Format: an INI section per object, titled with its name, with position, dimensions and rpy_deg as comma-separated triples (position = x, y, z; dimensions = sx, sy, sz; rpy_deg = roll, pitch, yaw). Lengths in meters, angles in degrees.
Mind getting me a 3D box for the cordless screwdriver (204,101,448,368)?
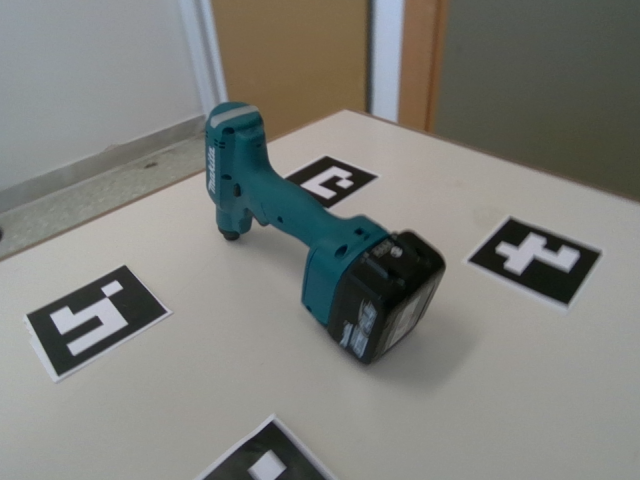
[cordless screwdriver]
position = -0.021, 0.002, 0.385
dimensions = 0.074, 0.159, 0.250
rpy_deg = -29, 59, -34
